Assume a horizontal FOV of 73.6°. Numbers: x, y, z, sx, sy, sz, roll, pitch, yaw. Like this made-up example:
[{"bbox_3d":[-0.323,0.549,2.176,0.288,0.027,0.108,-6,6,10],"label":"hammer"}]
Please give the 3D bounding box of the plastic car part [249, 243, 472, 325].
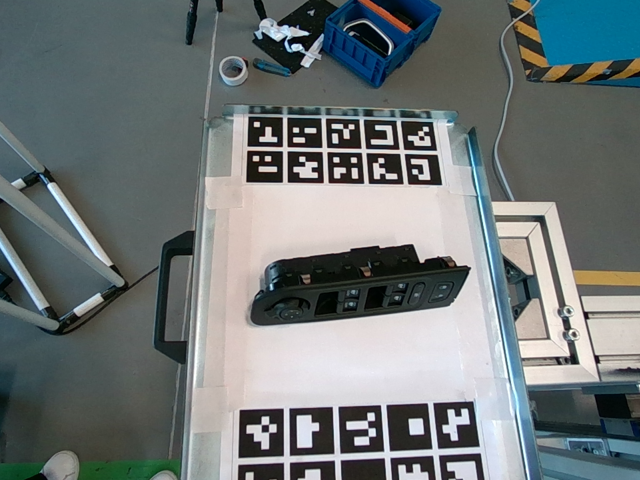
[{"bbox_3d":[0.031,0.038,0.405,0.203,0.067,0.066,-10,-30,-9],"label":"plastic car part"}]
